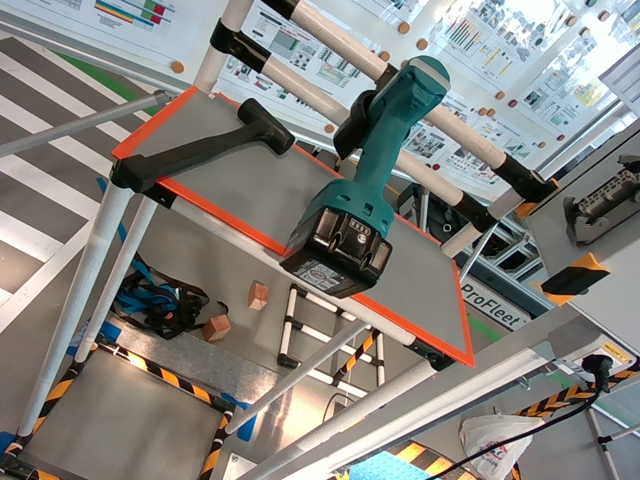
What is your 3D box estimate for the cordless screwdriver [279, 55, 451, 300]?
[{"bbox_3d":[0.042,-0.062,0.448,0.074,0.248,0.159,31,-22,-12],"label":"cordless screwdriver"}]
